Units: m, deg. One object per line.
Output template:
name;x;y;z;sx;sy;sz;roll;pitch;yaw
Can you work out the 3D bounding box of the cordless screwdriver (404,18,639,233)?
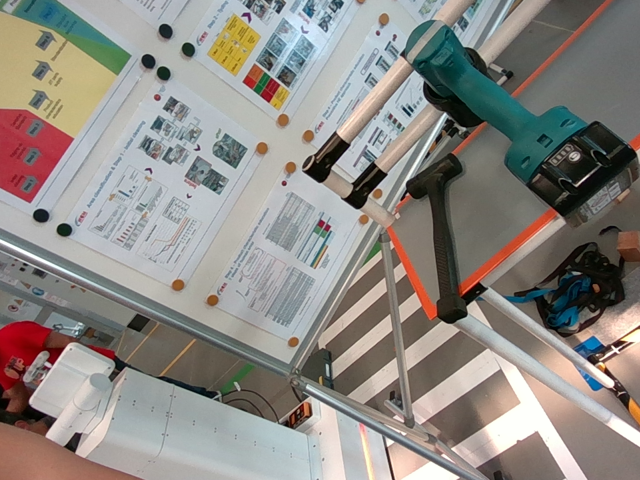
cordless screwdriver;0.199;-0.119;0.436;0.074;0.248;0.159;-47;-31;22
